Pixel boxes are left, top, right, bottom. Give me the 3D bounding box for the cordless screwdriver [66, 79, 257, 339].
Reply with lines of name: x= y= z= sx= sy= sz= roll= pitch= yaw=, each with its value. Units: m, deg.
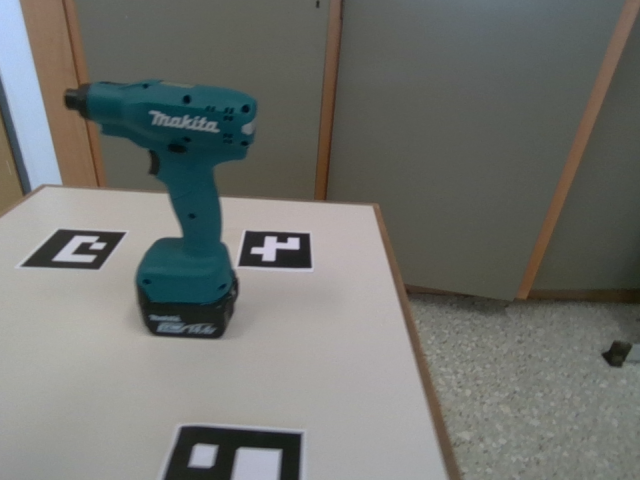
cordless screwdriver: x=-0.149 y=-0.025 z=0.414 sx=0.159 sy=0.249 sz=0.074 roll=8 pitch=28 yaw=-2
